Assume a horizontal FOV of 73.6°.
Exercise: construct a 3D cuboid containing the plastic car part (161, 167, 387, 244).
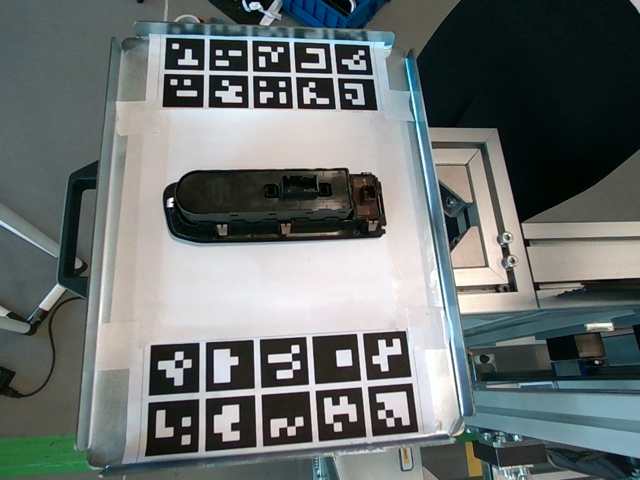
[{"bbox_3d":[-0.038,-0.033,0.375,0.203,0.066,0.067,-4,-11,-6],"label":"plastic car part"}]
